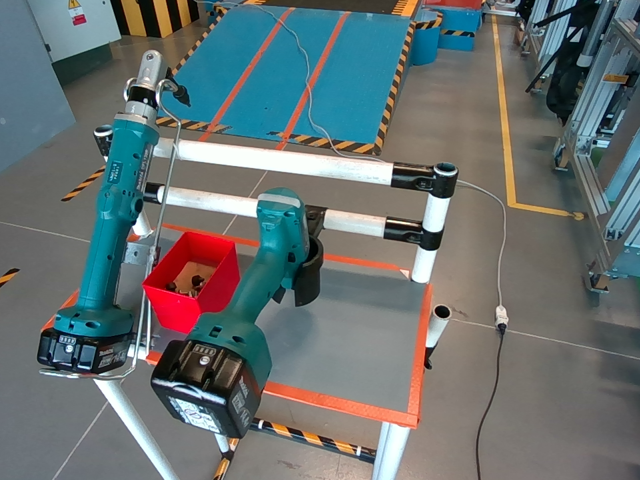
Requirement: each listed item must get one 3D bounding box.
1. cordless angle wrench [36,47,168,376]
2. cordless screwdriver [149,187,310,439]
[{"bbox_3d":[-0.260,-0.048,0.551,0.074,0.422,0.098,11,-4,4],"label":"cordless angle wrench"},{"bbox_3d":[-0.069,0.079,0.457,0.074,0.248,0.159,10,-39,15],"label":"cordless screwdriver"}]
